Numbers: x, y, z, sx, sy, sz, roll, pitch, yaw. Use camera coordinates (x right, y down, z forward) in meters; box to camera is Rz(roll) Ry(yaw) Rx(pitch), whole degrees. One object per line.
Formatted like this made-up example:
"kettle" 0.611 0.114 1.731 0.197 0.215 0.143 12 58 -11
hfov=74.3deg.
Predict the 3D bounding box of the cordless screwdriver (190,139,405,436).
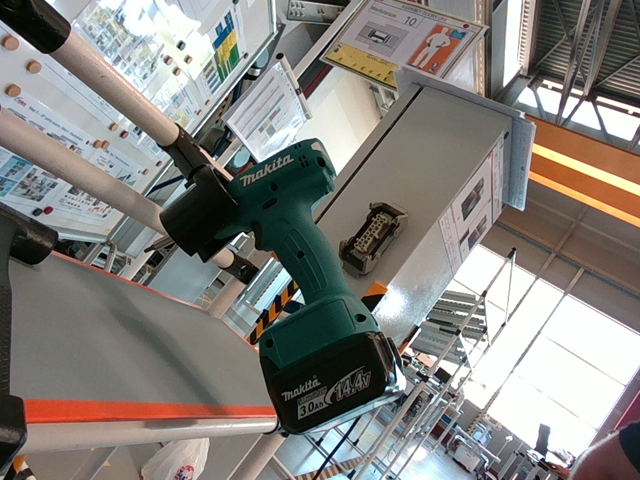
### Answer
"cordless screwdriver" -0.035 0.038 0.370 0.159 0.248 0.074 -24 -27 11
